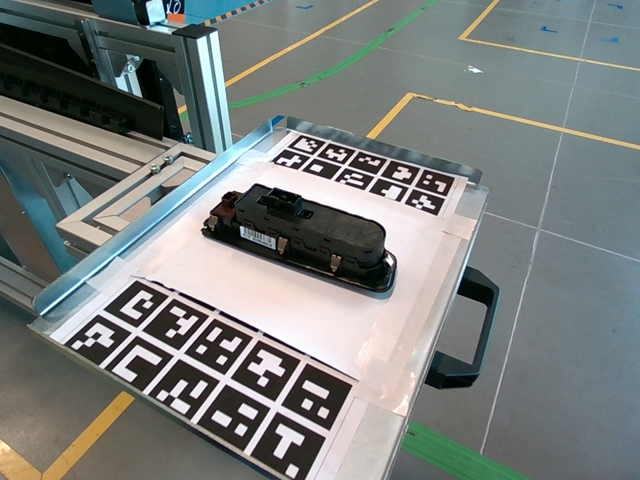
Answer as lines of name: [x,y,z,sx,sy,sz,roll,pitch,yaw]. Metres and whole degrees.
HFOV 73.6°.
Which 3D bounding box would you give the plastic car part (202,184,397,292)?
plastic car part: [-0.017,-0.012,0.421,0.204,0.067,0.066,22,39,15]
